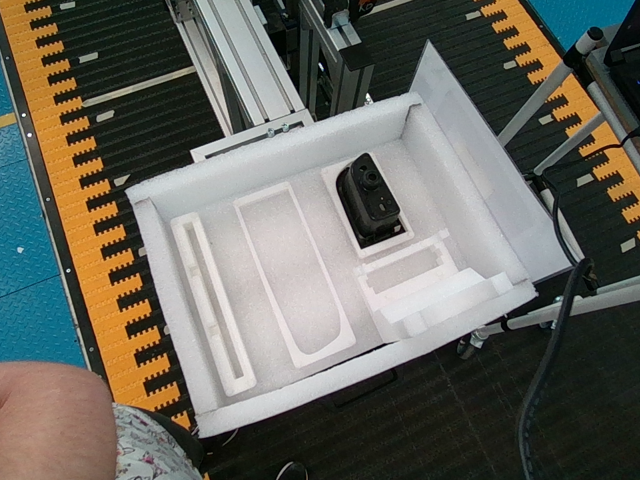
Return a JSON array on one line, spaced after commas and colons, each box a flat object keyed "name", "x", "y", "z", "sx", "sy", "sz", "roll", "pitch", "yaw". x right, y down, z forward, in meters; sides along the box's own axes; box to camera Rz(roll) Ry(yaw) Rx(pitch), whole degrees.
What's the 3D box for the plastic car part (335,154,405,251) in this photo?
[{"name": "plastic car part", "x": 0.061, "y": -0.057, "z": 0.535, "sx": 0.066, "sy": 0.116, "sz": 0.071, "roll": -20, "pitch": -13, "yaw": -11}]
